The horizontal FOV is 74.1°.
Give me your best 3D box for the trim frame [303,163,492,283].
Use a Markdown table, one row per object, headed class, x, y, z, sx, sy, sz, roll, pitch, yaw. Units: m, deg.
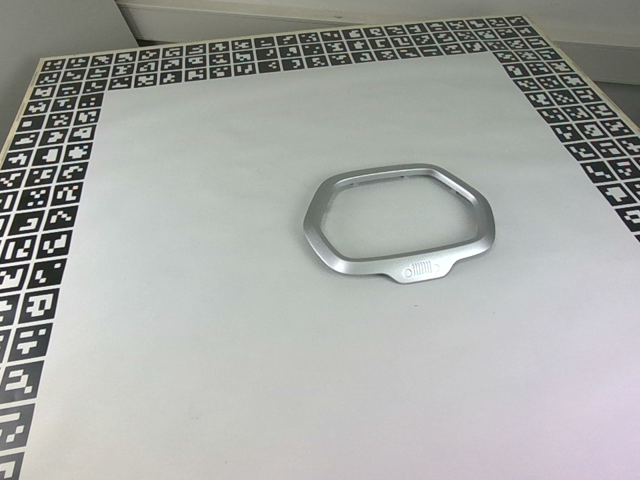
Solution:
| class | x | y | z | sx | sy | sz | roll | pitch | yaw |
| --- | --- | --- | --- | --- | --- | --- | --- | --- | --- |
| trim frame | 0.100 | -0.030 | 0.553 | 0.248 | 0.184 | 0.027 | -10 | -36 | -10 |
